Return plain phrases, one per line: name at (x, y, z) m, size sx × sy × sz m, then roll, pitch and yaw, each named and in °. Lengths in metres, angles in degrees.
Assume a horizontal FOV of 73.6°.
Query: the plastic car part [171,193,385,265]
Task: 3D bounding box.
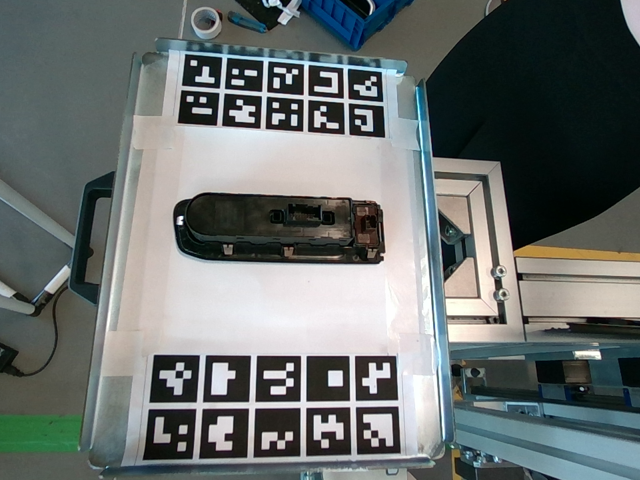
plastic car part at (-0.036, -0.012, 0.392) m, size 0.203 × 0.066 × 0.067 m, roll 0°, pitch -10°, yaw -5°
